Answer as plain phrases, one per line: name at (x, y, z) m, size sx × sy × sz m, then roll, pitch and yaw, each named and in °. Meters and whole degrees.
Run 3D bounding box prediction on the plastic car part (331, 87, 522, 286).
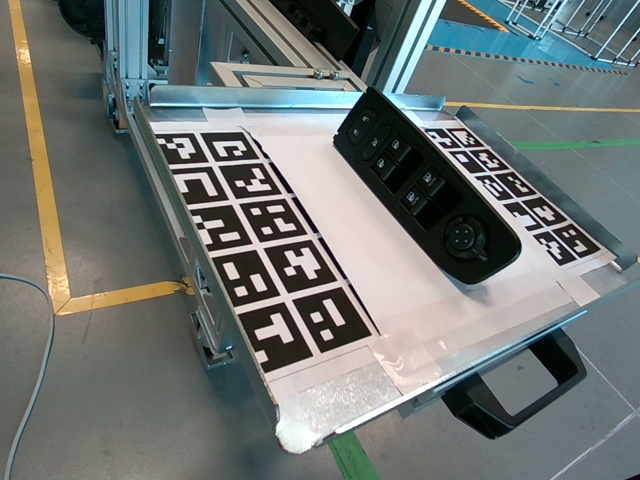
plastic car part at (0.091, -0.044, 0.374) m, size 0.067 × 0.203 × 0.067 m, roll -46°, pitch -35°, yaw 20°
